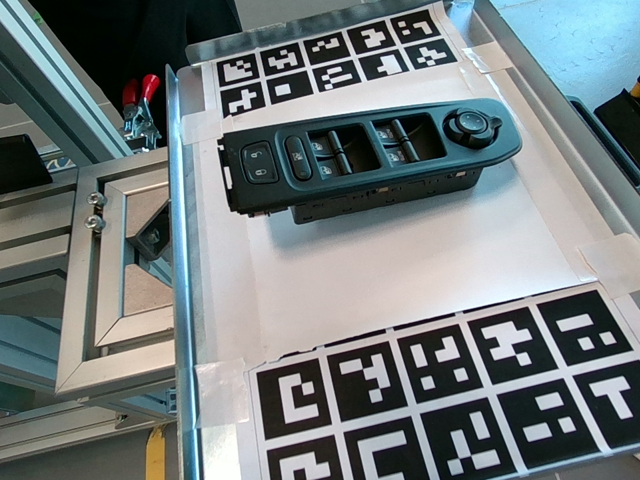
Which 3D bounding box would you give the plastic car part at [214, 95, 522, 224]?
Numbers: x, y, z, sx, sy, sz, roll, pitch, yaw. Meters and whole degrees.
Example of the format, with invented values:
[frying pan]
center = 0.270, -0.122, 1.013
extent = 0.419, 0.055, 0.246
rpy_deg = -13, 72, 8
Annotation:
[plastic car part]
center = 0.038, -0.049, 0.292
extent = 0.203, 0.066, 0.067
rpy_deg = -14, -37, -5
